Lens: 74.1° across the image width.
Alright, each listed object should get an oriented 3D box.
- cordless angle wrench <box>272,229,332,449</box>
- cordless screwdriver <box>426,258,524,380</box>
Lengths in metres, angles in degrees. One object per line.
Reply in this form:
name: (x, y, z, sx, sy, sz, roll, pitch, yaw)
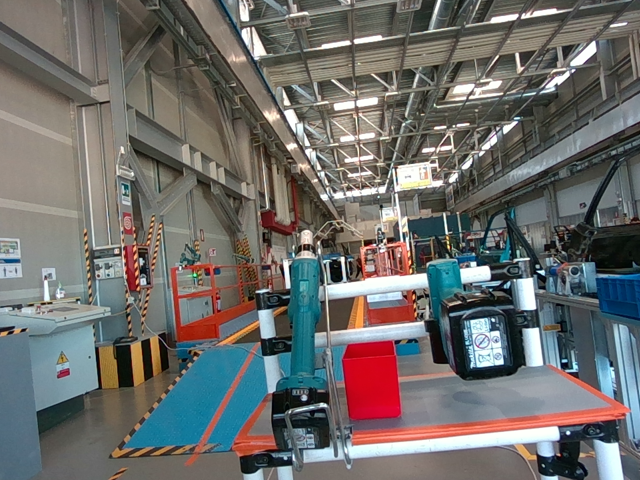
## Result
cordless angle wrench: (-0.025, 0.119, 0.709, 0.074, 0.098, 0.421, -3, 40, 2)
cordless screwdriver: (0.196, 0.120, 0.583, 0.074, 0.159, 0.248, -9, 6, 6)
